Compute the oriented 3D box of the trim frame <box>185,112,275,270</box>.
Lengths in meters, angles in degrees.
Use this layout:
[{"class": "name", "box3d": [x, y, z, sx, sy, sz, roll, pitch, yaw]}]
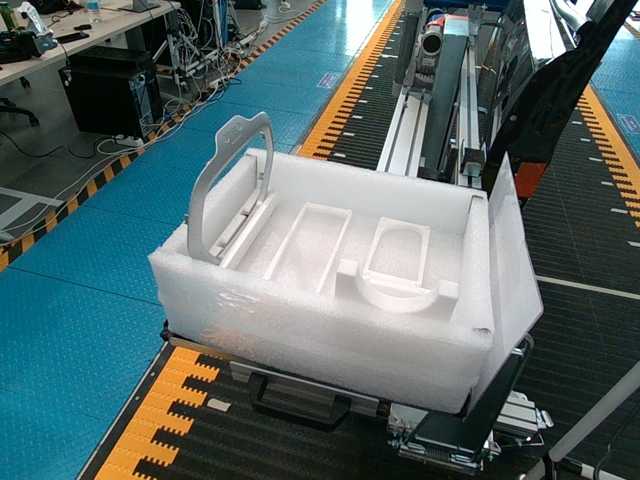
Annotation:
[{"class": "trim frame", "box3d": [-0.113, -0.070, 0.573, 0.027, 0.184, 0.247, 18, 46, 10]}]
